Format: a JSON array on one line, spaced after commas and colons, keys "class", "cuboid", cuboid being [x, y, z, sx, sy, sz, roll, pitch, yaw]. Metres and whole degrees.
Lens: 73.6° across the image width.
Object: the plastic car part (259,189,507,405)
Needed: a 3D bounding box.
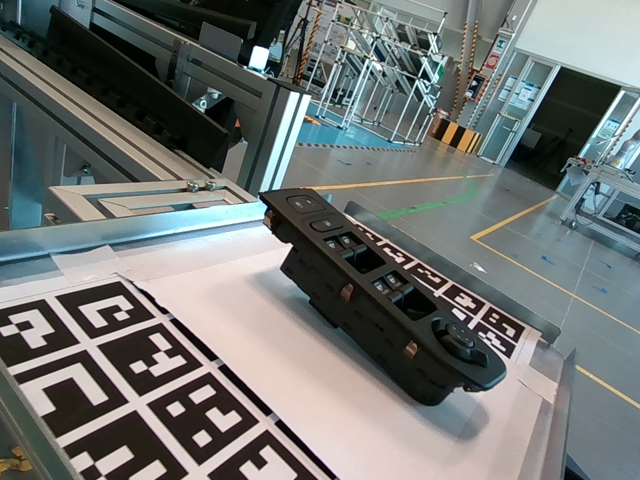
[{"class": "plastic car part", "cuboid": [0.032, 0.040, 0.305, 0.203, 0.067, 0.066, 38, 19, 22]}]
